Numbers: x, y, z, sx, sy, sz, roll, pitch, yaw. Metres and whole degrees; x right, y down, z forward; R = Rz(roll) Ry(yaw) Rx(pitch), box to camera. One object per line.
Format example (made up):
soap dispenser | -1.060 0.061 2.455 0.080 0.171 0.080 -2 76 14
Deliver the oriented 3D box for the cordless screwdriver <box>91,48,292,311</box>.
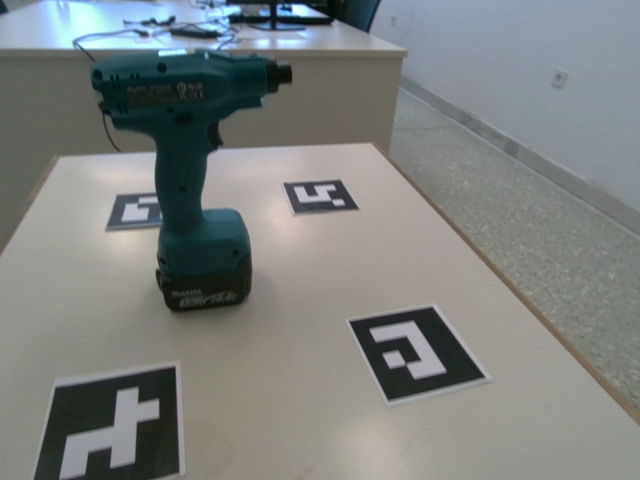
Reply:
cordless screwdriver | -0.102 -0.051 0.414 0.158 0.248 0.075 -8 34 -10
